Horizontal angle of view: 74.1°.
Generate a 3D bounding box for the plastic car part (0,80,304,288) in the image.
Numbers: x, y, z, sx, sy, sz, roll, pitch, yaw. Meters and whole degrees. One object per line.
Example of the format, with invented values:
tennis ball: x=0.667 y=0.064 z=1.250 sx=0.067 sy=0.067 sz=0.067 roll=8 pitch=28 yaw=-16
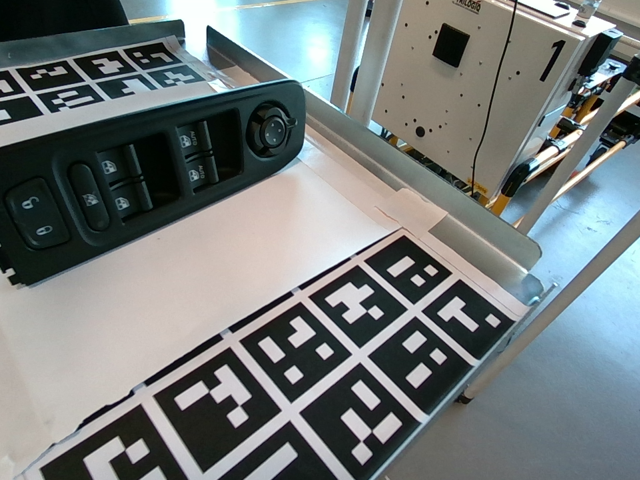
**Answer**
plastic car part: x=-0.094 y=-0.050 z=0.262 sx=0.202 sy=0.067 sz=0.068 roll=-29 pitch=31 yaw=-31
